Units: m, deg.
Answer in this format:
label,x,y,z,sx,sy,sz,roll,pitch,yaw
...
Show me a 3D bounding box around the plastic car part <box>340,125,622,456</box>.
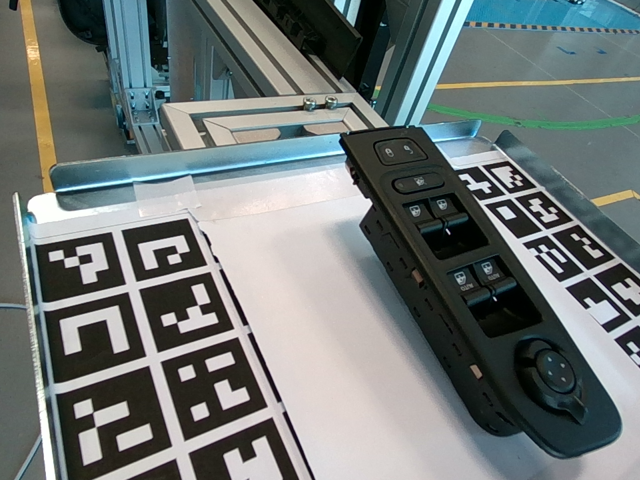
label,x,y,z,sx,sy,sz,roll,pitch,yaw
plastic car part,0.073,0.023,0.244,0.066,0.203,0.067,-9,-34,-35
